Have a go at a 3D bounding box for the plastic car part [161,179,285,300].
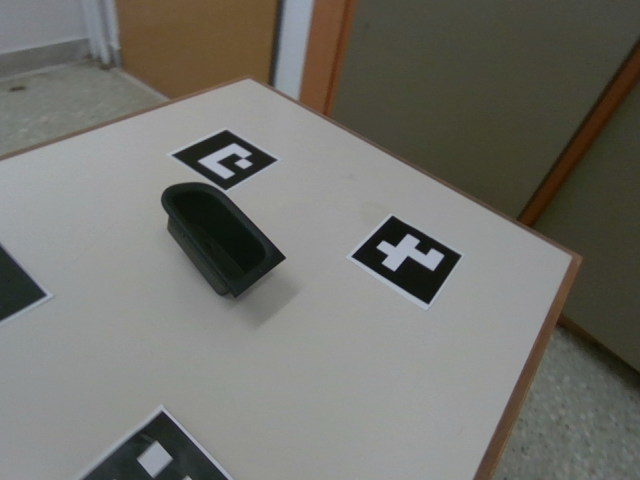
[{"bbox_3d":[-0.102,0.002,0.409,0.065,0.117,0.071,-38,-7,-34],"label":"plastic car part"}]
